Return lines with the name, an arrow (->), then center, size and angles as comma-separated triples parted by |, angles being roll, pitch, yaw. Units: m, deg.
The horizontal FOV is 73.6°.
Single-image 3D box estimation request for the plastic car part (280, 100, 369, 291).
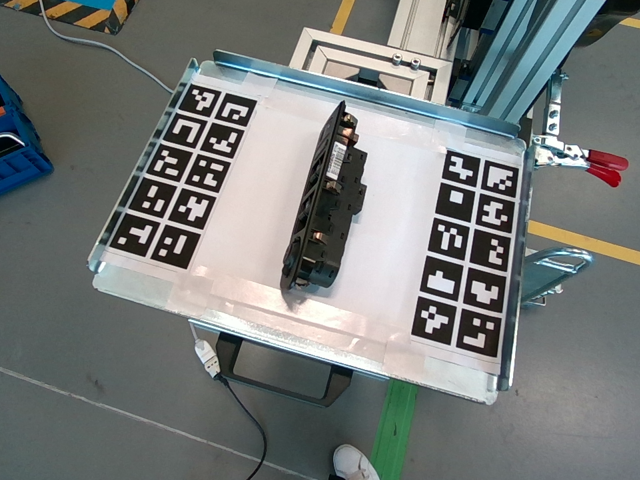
plastic car part -> 0.008, -0.036, 0.433 | 0.067, 0.202, 0.067 | 28, -25, -20
